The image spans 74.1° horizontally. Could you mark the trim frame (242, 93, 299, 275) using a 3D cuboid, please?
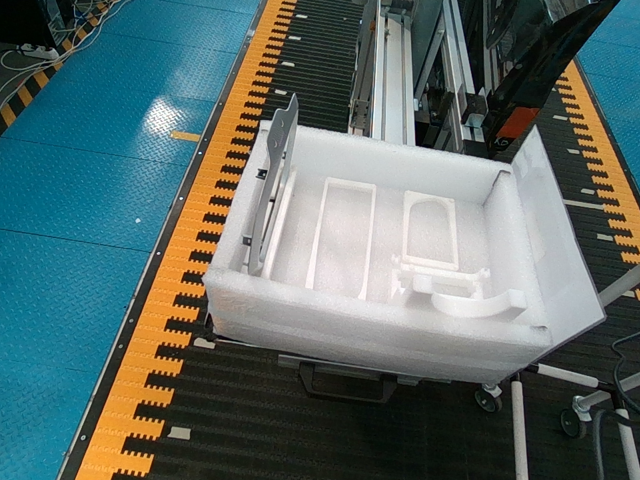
[{"bbox_3d":[-0.058,-0.069,0.525,0.027,0.247,0.185,15,-34,-2],"label":"trim frame"}]
